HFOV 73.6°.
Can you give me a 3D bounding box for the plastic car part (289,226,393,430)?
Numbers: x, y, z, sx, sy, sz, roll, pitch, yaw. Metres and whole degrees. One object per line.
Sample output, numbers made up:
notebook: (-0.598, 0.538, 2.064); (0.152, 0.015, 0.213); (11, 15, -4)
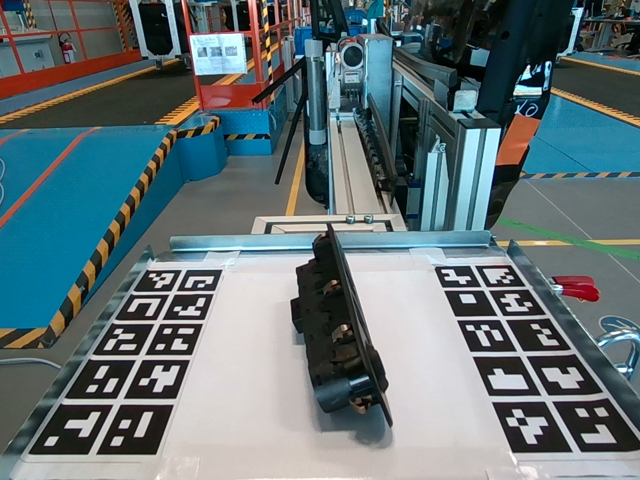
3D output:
plastic car part: (0.010, 0.061, 0.345); (0.067, 0.066, 0.203); (-15, 27, -3)
